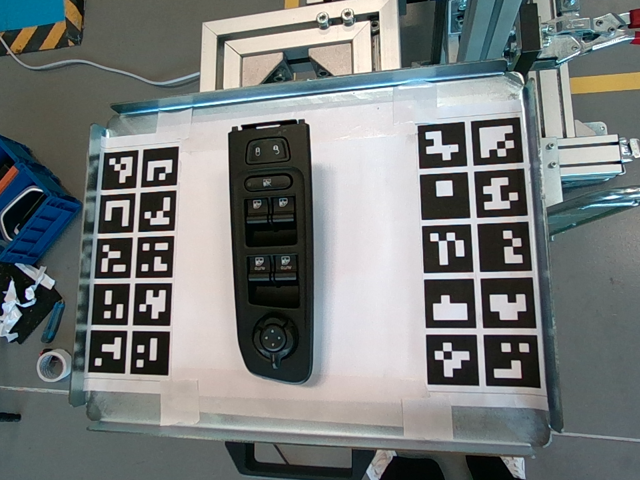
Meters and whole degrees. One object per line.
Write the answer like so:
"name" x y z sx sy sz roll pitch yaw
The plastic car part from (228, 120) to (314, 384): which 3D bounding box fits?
"plastic car part" -0.036 0.011 0.351 0.066 0.202 0.067 -2 -5 4
